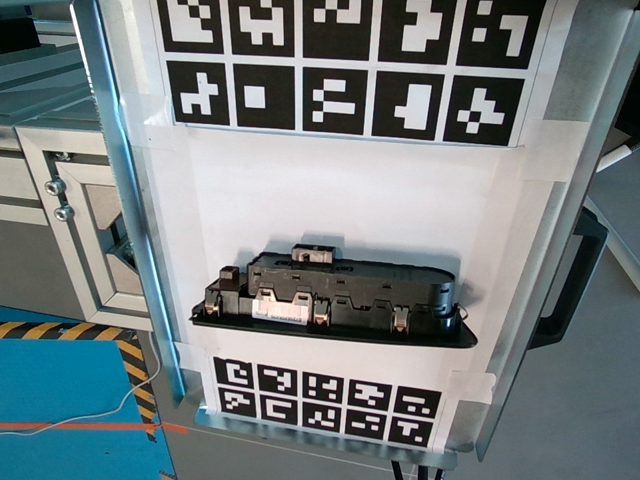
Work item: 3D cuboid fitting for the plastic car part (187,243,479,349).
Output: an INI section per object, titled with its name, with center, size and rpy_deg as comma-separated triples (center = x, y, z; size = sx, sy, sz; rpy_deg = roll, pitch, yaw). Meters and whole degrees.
[plastic car part]
center = 0.012, 0.039, 0.317
size = 0.203, 0.067, 0.066
rpy_deg = 9, 6, 8
